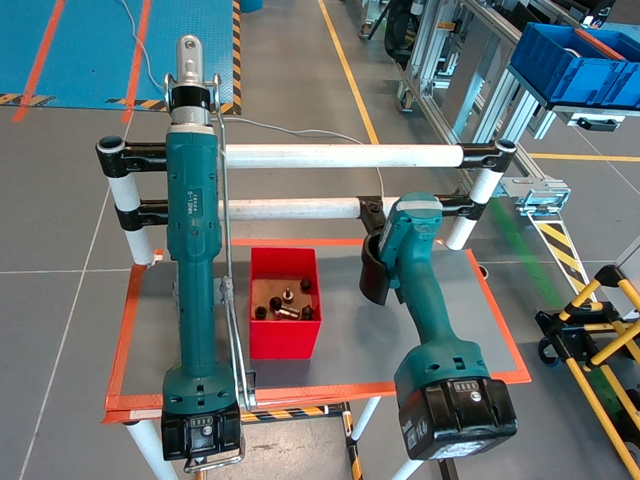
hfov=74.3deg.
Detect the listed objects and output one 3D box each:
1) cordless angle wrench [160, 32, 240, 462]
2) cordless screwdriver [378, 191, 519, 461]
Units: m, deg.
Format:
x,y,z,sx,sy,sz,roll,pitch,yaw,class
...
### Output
x,y,z,sx,sy,sz,roll,pitch,yaw,class
-0.130,-0.001,0.439,0.074,0.423,0.098,-2,0,-18,cordless angle wrench
0.105,0.090,0.442,0.074,0.248,0.160,-1,-34,-8,cordless screwdriver
